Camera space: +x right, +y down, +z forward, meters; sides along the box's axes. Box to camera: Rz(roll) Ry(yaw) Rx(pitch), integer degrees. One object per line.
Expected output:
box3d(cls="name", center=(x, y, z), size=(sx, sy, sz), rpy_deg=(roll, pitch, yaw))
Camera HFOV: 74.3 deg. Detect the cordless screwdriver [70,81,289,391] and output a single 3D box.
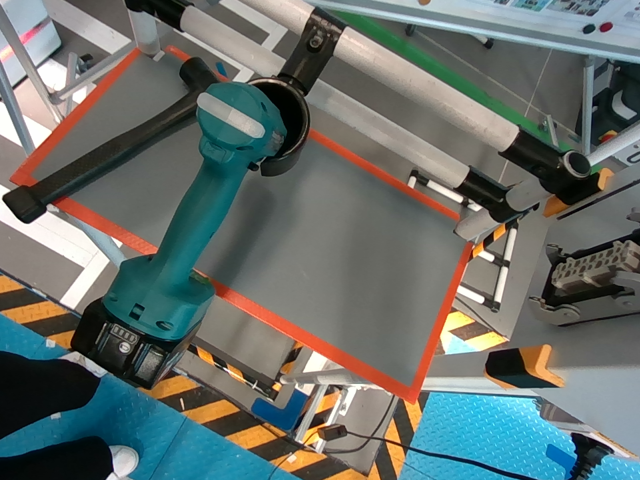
box3d(cls="cordless screwdriver", center=(-0.102, -0.008, 0.368), size=(0.074, 0.249, 0.159), rpy_deg=(30, 10, -1))
